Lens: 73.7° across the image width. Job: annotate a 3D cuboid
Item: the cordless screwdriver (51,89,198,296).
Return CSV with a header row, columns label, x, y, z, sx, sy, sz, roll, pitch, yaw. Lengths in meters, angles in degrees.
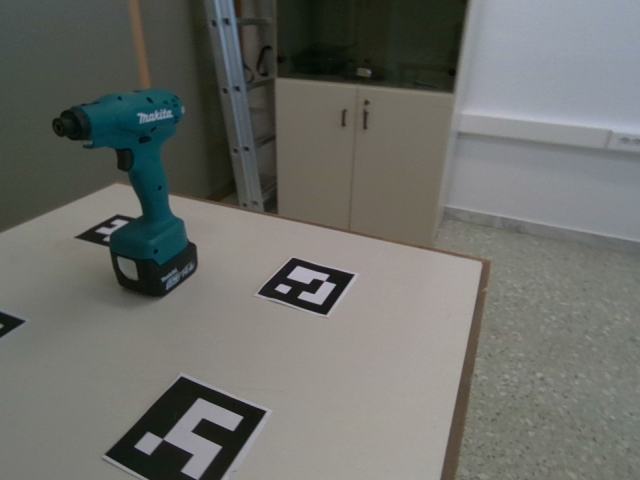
label,x,y,z,sx,sy,sz,roll,pitch,yaw
cordless screwdriver,-0.227,-0.048,0.518,0.075,0.249,0.158,13,27,20
